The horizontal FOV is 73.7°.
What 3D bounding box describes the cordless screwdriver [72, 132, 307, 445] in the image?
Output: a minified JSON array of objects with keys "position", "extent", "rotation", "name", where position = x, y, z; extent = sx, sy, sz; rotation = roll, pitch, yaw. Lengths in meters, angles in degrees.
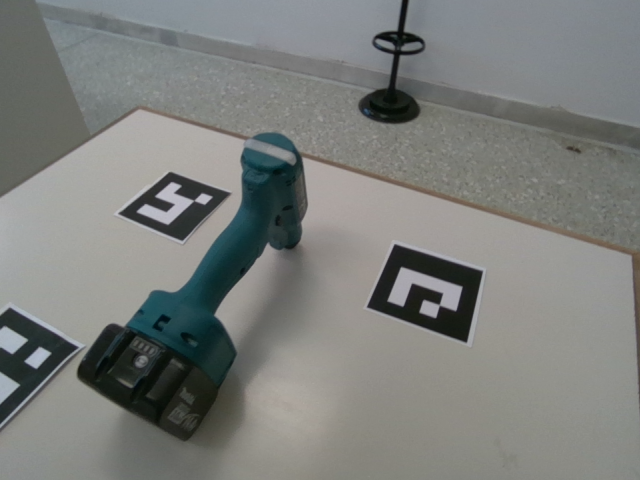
[{"position":[-0.082,0.042,0.377],"extent":[0.075,0.248,0.159],"rotation":[21,-27,14],"name":"cordless screwdriver"}]
